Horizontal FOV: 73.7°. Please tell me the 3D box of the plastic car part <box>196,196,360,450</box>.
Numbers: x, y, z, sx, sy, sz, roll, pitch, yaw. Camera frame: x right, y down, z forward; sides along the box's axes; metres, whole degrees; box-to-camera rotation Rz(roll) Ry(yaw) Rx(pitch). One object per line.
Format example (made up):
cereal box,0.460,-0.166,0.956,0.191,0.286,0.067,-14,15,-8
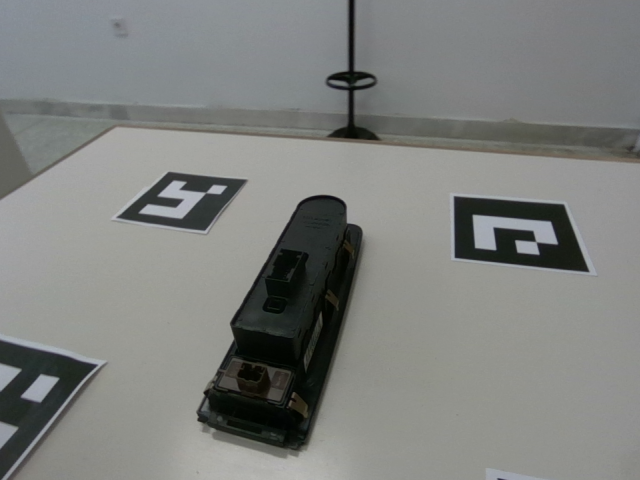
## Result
plastic car part,-0.018,0.031,0.300,0.067,0.067,0.202,1,34,18
